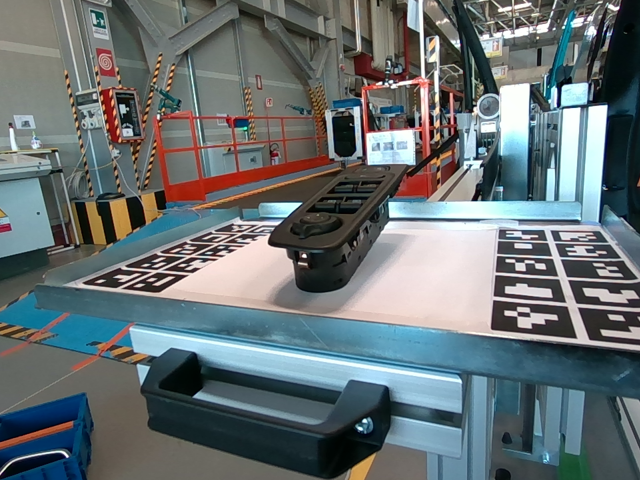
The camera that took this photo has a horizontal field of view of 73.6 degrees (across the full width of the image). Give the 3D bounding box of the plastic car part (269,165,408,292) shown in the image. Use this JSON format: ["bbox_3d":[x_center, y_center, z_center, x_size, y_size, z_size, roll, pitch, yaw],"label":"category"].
[{"bbox_3d":[0.020,-0.016,0.359,0.066,0.067,0.202,9,23,20],"label":"plastic car part"}]
